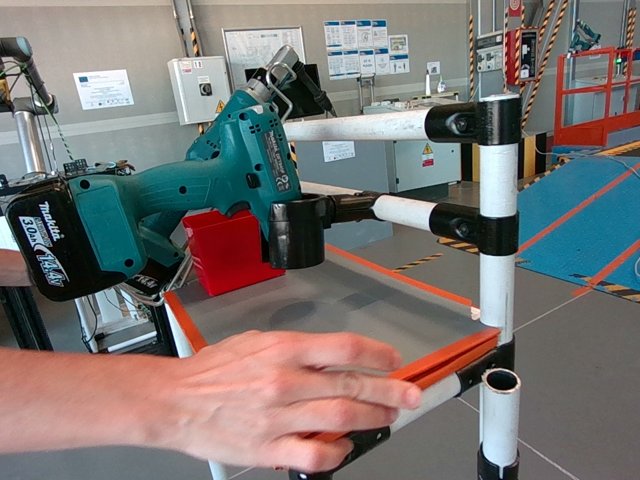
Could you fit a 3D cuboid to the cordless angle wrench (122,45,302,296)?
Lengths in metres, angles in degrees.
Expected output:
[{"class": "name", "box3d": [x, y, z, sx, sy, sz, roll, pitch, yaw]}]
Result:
[{"class": "cordless angle wrench", "box3d": [-0.158, -0.120, 0.620, 0.098, 0.422, 0.074, 40, -10, -38]}]

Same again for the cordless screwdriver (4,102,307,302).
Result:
[{"class": "cordless screwdriver", "box3d": [-0.129, -0.018, 0.397, 0.248, 0.159, 0.074, -25, 21, -23]}]
